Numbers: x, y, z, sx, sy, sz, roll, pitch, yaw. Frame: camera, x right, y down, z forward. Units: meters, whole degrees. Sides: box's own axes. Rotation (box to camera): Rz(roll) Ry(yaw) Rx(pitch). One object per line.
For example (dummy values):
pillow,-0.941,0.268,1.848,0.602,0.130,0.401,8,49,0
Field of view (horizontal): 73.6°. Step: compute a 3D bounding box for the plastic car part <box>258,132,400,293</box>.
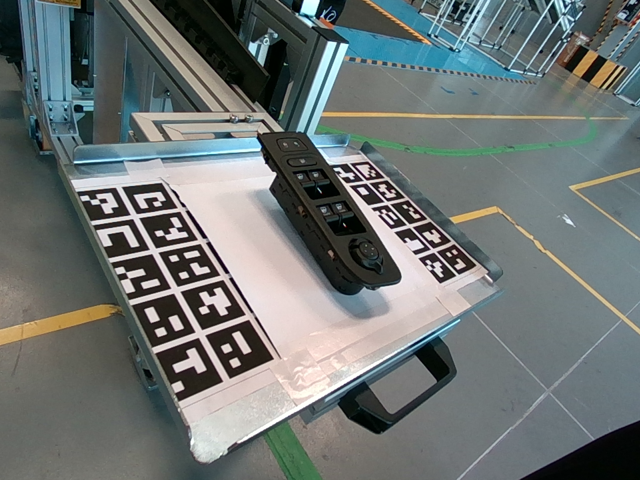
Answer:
plastic car part,0.000,-0.024,0.440,0.066,0.203,0.067,-10,-35,-48
